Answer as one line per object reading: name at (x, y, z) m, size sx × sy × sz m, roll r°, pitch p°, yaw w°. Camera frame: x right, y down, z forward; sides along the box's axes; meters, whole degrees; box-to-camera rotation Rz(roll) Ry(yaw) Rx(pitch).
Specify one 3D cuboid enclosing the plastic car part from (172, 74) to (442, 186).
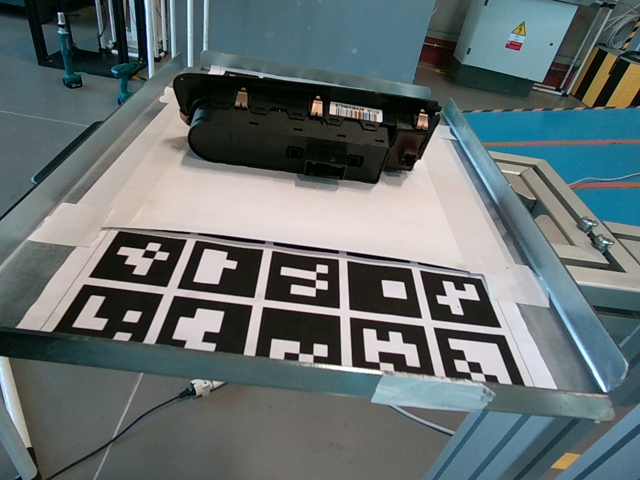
plastic car part at (-0.014, -0.078, 0.328) m, size 0.203 × 0.067 × 0.067 m, roll 10°, pitch -26°, yaw -3°
